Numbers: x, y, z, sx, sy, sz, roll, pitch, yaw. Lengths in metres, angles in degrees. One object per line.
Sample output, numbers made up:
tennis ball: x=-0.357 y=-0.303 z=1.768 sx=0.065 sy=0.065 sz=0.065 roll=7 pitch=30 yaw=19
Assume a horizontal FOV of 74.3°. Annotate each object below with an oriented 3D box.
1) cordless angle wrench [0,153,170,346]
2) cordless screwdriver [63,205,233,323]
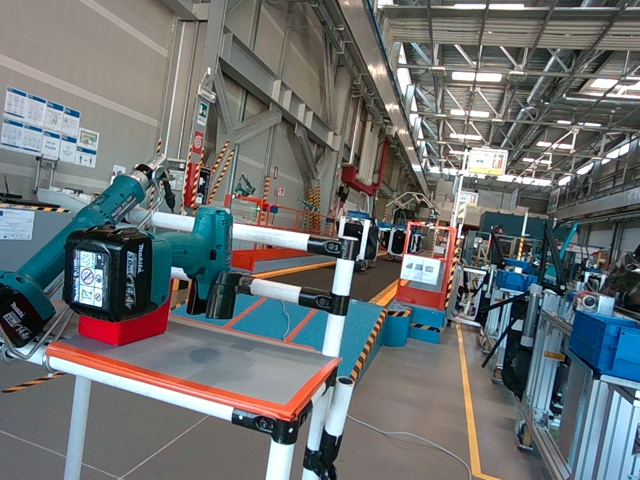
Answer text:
cordless angle wrench: x=-0.379 y=-0.025 z=0.707 sx=0.074 sy=0.098 sz=0.421 roll=14 pitch=47 yaw=13
cordless screwdriver: x=-0.189 y=0.044 z=0.534 sx=0.074 sy=0.159 sz=0.248 roll=7 pitch=11 yaw=18
